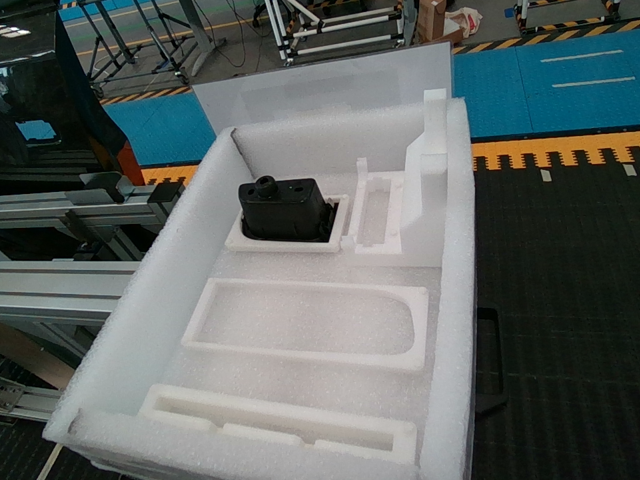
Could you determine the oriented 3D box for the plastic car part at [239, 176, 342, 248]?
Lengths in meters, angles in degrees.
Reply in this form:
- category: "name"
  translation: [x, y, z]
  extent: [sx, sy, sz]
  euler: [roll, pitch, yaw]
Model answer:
- category: "plastic car part"
  translation: [-0.043, -0.037, 0.463]
  extent: [0.117, 0.065, 0.071]
  euler: [3, -43, 18]
